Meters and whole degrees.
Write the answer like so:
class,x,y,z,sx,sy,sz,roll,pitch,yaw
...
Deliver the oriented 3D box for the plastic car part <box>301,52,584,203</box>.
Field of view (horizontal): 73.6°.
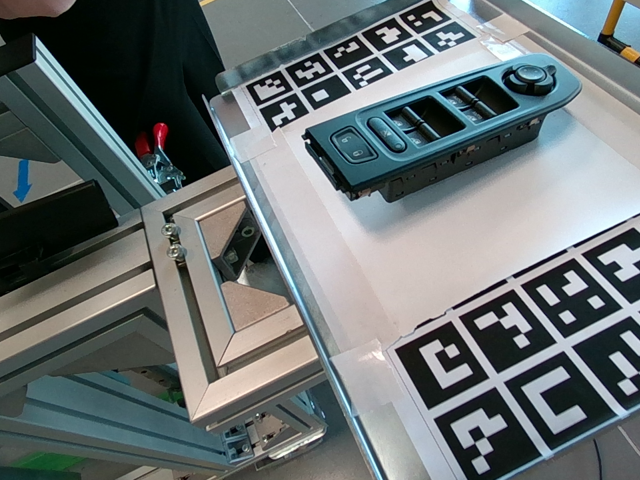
class,x,y,z,sx,sy,sz,roll,pitch,yaw
plastic car part,0.094,-0.075,0.306,0.203,0.067,0.066,-26,49,-8
